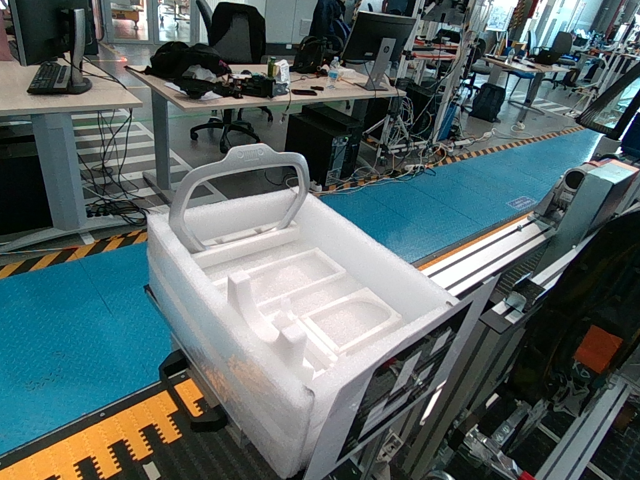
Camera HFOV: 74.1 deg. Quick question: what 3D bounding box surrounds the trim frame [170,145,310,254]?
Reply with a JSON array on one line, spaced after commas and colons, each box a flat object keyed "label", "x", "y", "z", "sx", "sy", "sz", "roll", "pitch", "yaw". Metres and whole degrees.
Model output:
[{"label": "trim frame", "x": -0.118, "y": -0.062, "z": 0.676, "sx": 0.247, "sy": 0.185, "sz": 0.027, "roll": -15, "pitch": 47, "yaw": -32}]
